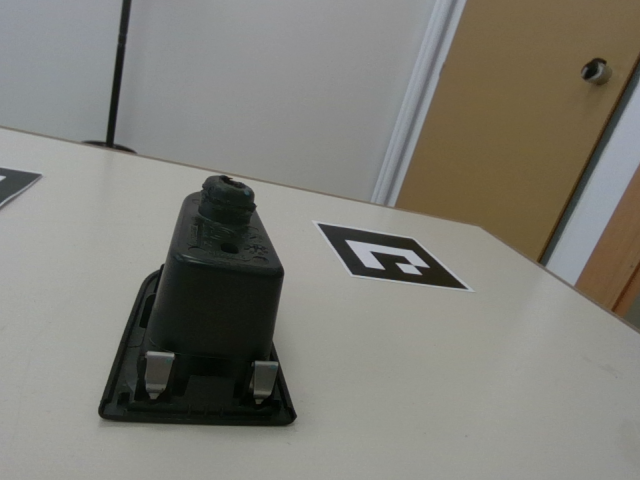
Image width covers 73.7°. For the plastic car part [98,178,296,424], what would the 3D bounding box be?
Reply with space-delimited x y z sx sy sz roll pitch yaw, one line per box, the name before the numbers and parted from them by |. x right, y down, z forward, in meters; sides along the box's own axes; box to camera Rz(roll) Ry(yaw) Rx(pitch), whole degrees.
plastic car part | -0.045 0.011 0.186 0.065 0.071 0.117 10 23 -18
